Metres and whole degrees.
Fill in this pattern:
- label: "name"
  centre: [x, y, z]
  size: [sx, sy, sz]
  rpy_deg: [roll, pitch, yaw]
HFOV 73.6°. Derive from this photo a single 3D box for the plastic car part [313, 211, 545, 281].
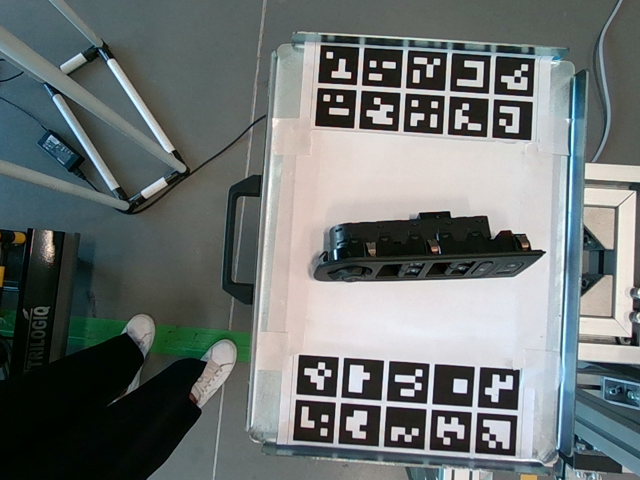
- label: "plastic car part"
  centre: [0.092, 0.006, 0.401]
  size: [0.203, 0.067, 0.066]
  rpy_deg: [-6, -12, -1]
